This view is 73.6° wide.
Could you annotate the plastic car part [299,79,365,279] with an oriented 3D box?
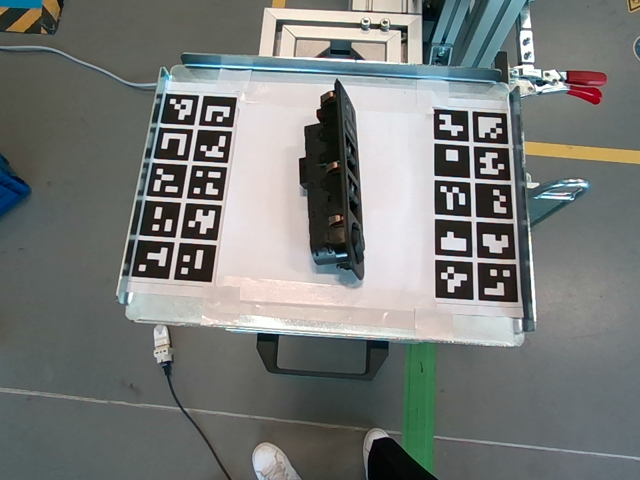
[{"bbox_3d":[0.013,-0.058,0.439,0.067,0.202,0.066,-10,-17,10],"label":"plastic car part"}]
